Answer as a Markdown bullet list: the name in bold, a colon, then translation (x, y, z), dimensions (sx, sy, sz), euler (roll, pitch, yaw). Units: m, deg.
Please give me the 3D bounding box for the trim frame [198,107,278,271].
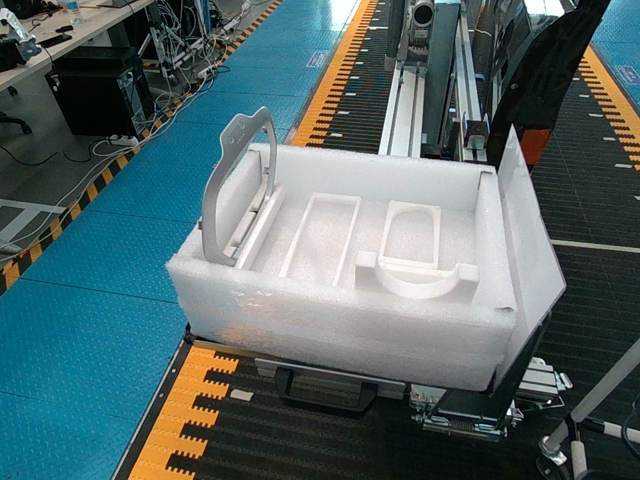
- **trim frame**: translation (-0.102, -0.072, 0.569), dimensions (0.027, 0.247, 0.184), euler (14, -42, 10)
